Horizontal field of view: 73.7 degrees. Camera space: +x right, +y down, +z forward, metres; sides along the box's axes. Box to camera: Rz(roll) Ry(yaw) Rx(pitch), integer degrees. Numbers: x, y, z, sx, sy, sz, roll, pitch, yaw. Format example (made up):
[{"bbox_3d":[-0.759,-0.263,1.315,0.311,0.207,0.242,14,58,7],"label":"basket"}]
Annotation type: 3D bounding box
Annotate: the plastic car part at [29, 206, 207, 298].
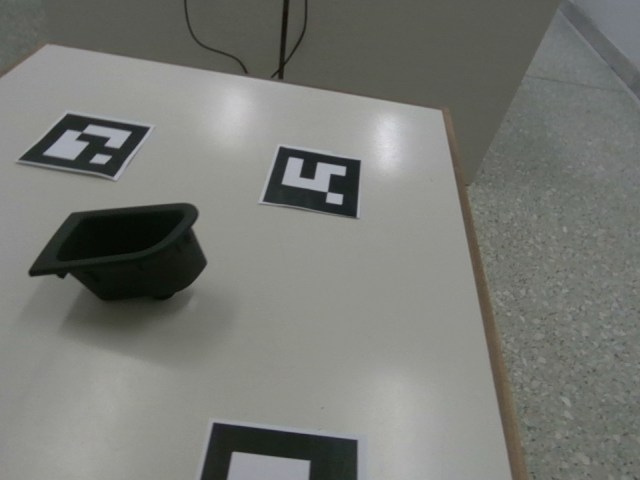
[{"bbox_3d":[-0.140,0.017,0.329,0.117,0.066,0.071,-1,-39,12],"label":"plastic car part"}]
